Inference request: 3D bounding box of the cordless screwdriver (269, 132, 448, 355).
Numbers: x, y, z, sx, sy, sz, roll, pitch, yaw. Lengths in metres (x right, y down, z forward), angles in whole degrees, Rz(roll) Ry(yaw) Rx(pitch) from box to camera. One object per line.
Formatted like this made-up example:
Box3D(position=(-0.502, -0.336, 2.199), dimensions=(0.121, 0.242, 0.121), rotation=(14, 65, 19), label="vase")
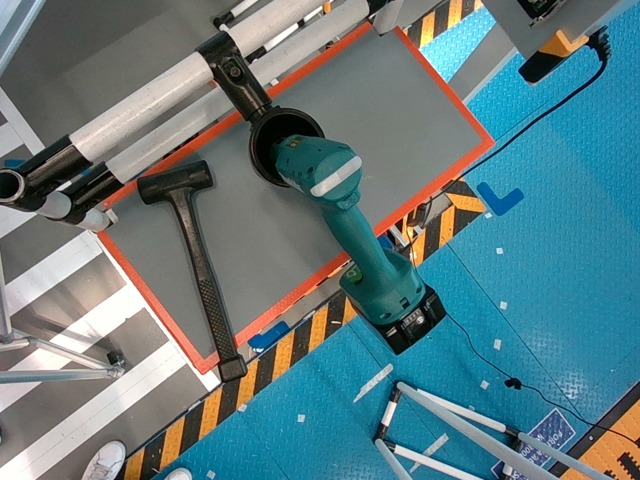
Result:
Box3D(position=(0.031, -0.003, 0.447), dimensions=(0.074, 0.249, 0.159), rotation=(-37, 30, -7), label="cordless screwdriver")
